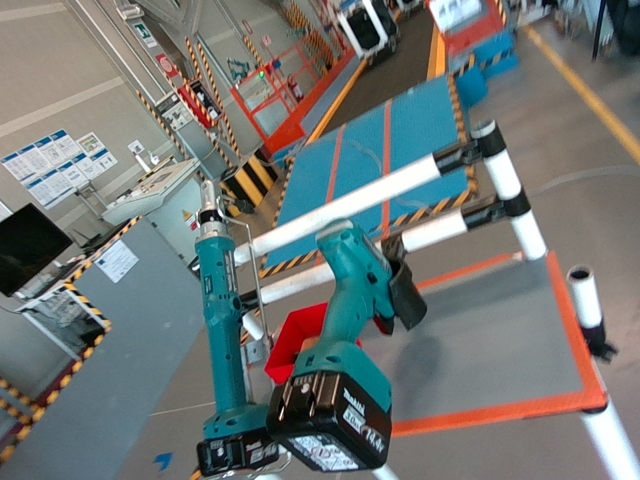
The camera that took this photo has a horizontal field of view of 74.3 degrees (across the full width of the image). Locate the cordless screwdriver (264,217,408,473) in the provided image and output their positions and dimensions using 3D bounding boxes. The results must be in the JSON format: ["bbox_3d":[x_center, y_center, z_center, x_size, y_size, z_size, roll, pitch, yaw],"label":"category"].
[{"bbox_3d":[0.041,0.106,0.439,0.074,0.248,0.159,-23,-56,32],"label":"cordless screwdriver"}]

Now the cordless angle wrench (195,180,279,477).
[{"bbox_3d":[-0.140,0.101,0.615,0.074,0.422,0.098,-19,-20,21],"label":"cordless angle wrench"}]
